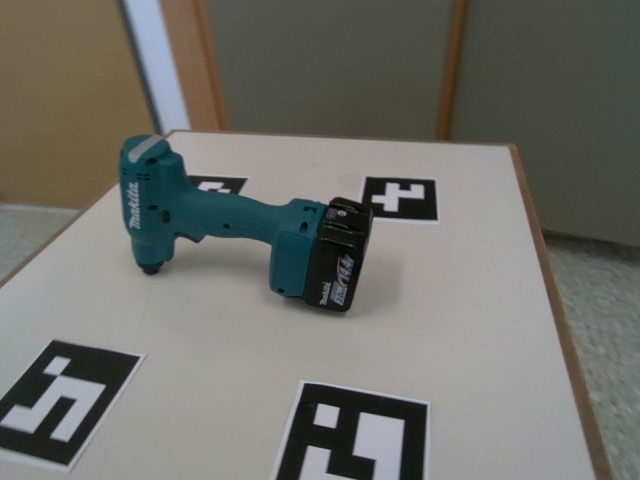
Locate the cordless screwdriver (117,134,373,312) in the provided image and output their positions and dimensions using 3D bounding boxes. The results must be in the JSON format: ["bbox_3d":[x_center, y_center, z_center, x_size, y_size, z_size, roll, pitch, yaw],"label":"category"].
[{"bbox_3d":[-0.081,0.004,0.427,0.249,0.159,0.074,18,37,4],"label":"cordless screwdriver"}]
